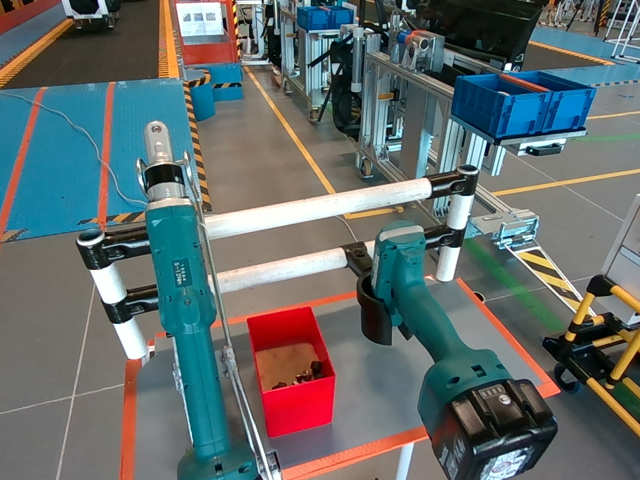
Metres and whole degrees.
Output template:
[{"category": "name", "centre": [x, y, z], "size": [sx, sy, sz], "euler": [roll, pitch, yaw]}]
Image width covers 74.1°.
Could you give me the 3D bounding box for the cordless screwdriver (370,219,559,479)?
[{"category": "cordless screwdriver", "centre": [0.112, 0.113, 0.431], "size": [0.074, 0.159, 0.248], "euler": [-11, 45, -12]}]

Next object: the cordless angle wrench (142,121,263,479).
[{"category": "cordless angle wrench", "centre": [-0.134, 0.071, 0.431], "size": [0.074, 0.422, 0.098], "euler": [-11, -12, -19]}]
